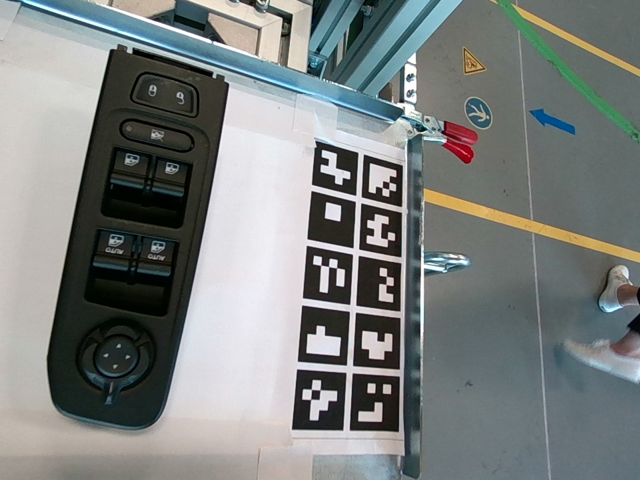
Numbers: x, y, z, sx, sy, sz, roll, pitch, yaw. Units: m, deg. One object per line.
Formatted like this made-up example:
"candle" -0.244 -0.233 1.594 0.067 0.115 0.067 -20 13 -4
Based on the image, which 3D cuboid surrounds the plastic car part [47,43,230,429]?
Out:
"plastic car part" -0.107 -0.001 0.247 0.066 0.202 0.067 12 -13 -30
